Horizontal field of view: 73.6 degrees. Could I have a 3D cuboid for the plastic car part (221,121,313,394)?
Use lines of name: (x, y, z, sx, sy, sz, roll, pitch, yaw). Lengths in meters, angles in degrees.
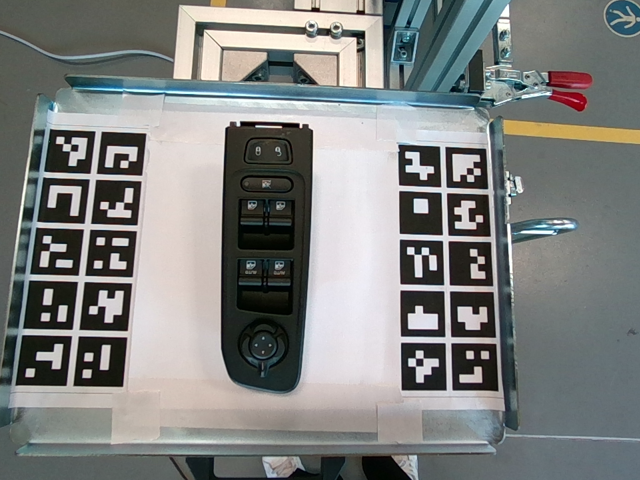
plastic car part: (-0.044, 0.014, 0.338, 0.066, 0.202, 0.067, 2, -6, -11)
